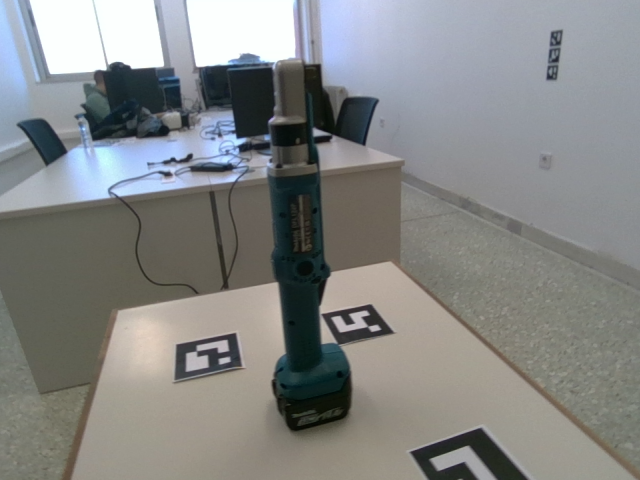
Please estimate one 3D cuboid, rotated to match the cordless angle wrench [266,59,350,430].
[{"bbox_3d":[-0.024,0.022,0.489,0.097,0.422,0.075,-9,22,-15],"label":"cordless angle wrench"}]
